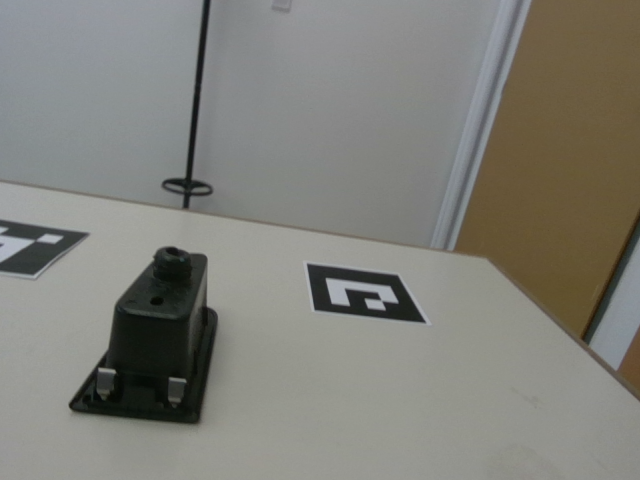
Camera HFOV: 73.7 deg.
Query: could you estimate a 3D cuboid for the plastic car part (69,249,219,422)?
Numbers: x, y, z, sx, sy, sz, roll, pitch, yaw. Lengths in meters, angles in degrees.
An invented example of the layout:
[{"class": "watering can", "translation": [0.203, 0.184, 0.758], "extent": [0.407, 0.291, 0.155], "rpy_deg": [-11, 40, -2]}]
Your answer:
[{"class": "plastic car part", "translation": [-0.095, 0.044, 0.267], "extent": [0.066, 0.071, 0.116], "rpy_deg": [9, 23, -7]}]
